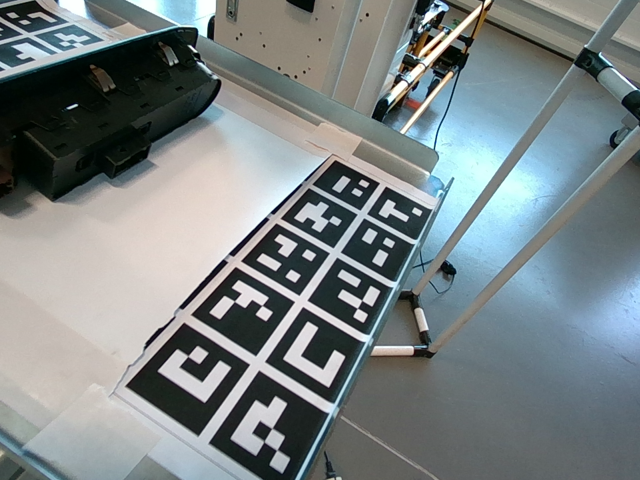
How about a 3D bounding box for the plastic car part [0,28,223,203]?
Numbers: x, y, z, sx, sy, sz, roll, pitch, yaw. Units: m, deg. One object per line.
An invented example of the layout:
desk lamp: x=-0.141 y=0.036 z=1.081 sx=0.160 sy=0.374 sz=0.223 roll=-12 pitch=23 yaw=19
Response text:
plastic car part: x=-0.128 y=-0.080 z=0.263 sx=0.067 sy=0.066 sz=0.202 roll=30 pitch=45 yaw=4
